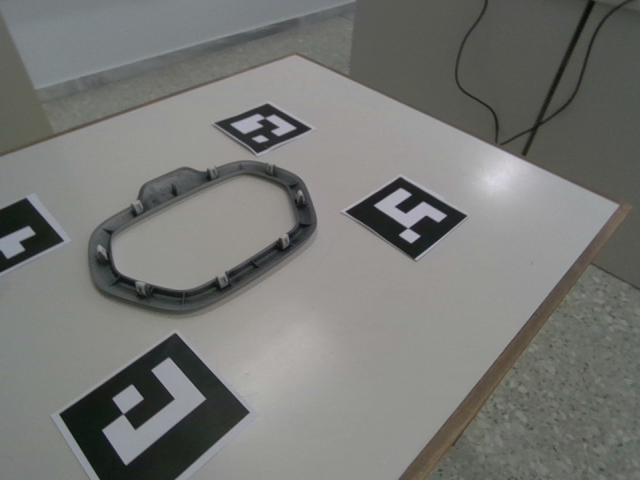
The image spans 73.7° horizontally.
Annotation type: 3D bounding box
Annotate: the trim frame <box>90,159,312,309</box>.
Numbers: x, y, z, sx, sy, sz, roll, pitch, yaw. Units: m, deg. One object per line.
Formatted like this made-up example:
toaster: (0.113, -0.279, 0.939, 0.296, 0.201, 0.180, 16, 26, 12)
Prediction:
trim frame: (-0.123, -0.021, 0.464, 0.246, 0.027, 0.185, -33, 55, -25)
